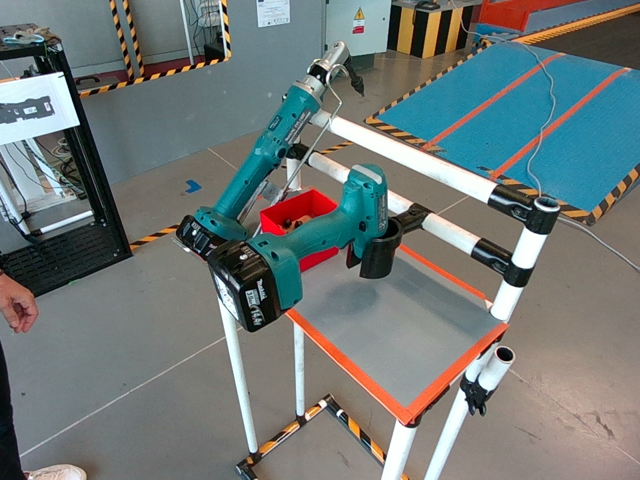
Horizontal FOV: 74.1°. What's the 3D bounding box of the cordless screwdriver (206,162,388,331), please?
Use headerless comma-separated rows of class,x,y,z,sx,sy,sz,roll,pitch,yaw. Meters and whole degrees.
cordless screwdriver,-0.009,0.020,0.543,0.248,0.159,0.074,-33,48,-22

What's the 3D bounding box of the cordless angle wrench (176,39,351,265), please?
cordless angle wrench,-0.079,-0.152,0.702,0.074,0.423,0.098,35,2,35
